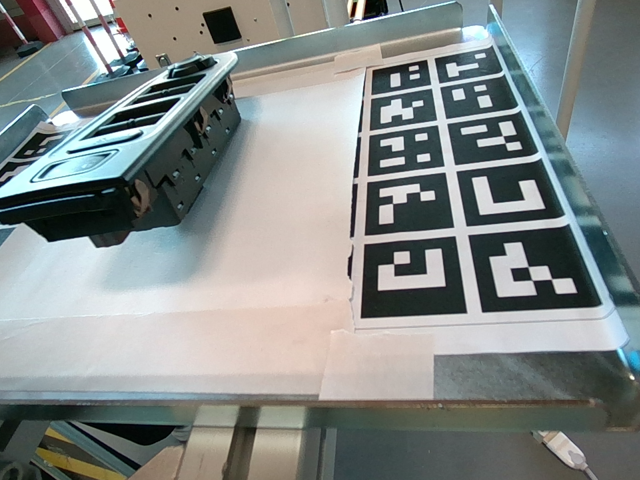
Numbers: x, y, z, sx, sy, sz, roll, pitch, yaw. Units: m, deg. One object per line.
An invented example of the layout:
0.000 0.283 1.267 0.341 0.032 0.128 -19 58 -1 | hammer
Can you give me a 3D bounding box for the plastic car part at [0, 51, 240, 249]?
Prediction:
-0.085 -0.060 0.246 0.066 0.067 0.202 -13 39 17 | plastic car part
